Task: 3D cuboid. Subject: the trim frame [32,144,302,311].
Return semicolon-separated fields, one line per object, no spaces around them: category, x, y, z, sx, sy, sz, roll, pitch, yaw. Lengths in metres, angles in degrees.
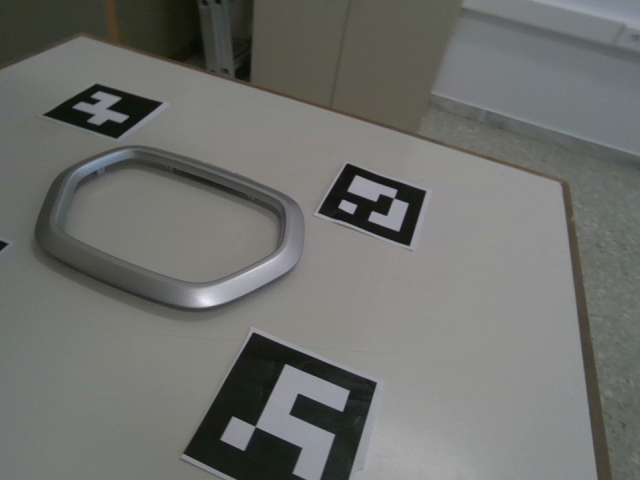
trim frame;-0.137;-0.024;0.397;0.249;0.027;0.183;18;48;10
